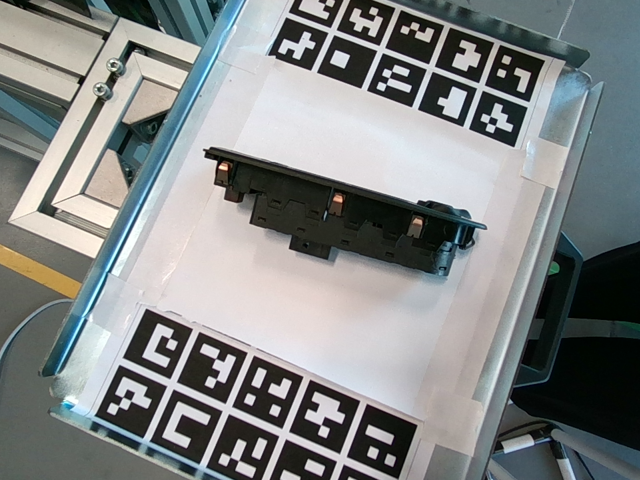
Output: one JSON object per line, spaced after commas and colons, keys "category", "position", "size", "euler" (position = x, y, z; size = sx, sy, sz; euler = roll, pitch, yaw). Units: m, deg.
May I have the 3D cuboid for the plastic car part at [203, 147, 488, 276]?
{"category": "plastic car part", "position": [0.017, -0.017, 0.307], "size": [0.203, 0.067, 0.066], "euler": [11, -2, 4]}
